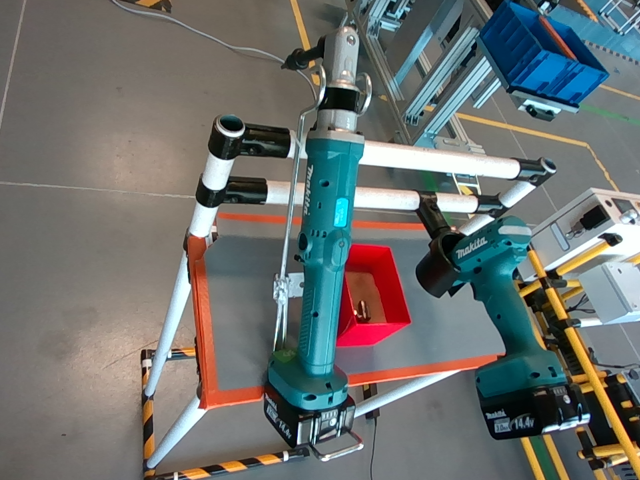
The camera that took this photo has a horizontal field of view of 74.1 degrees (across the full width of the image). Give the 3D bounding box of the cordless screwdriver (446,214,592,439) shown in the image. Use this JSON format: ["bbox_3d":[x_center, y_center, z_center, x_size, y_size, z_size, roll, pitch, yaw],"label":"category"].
[{"bbox_3d":[0.216,0.109,0.528,0.074,0.248,0.159,2,-23,-22],"label":"cordless screwdriver"}]

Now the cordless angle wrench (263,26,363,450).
[{"bbox_3d":[0.003,0.002,0.444,0.074,0.423,0.098,0,11,-32],"label":"cordless angle wrench"}]
